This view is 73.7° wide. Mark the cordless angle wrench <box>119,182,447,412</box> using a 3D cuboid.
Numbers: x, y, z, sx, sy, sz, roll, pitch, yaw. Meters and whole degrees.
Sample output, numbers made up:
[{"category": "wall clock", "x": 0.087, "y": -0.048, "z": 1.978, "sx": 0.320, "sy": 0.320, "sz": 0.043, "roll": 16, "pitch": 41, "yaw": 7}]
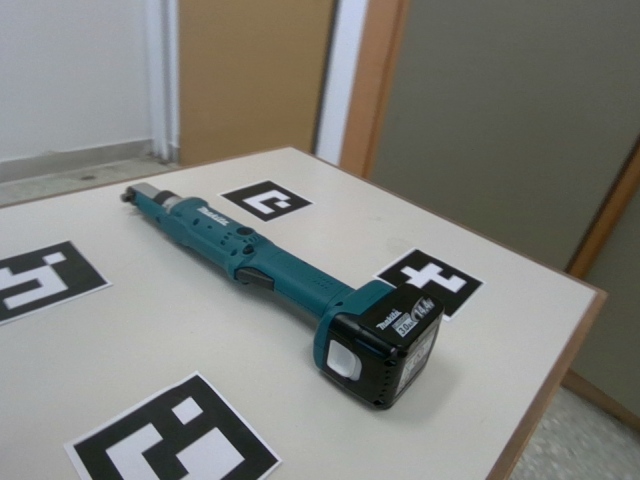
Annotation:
[{"category": "cordless angle wrench", "x": -0.081, "y": 0.015, "z": 0.455, "sx": 0.427, "sy": 0.074, "sz": 0.097, "roll": 27, "pitch": 34, "yaw": 31}]
